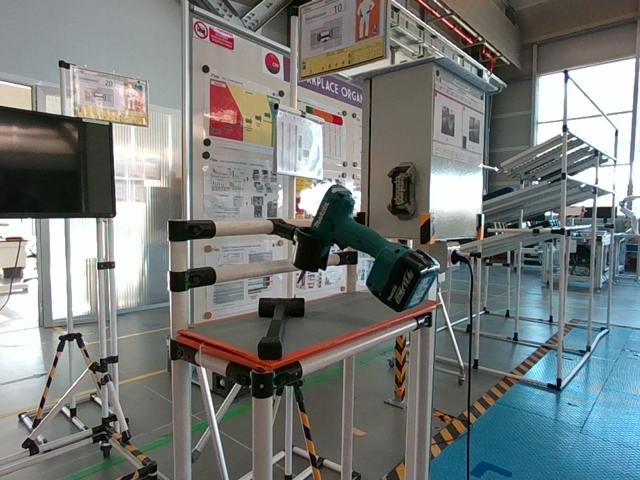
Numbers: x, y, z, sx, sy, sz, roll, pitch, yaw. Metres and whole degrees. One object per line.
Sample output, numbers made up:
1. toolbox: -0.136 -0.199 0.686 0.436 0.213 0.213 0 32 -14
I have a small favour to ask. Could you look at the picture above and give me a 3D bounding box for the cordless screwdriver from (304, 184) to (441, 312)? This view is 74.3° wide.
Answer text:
1. cordless screwdriver: 0.073 0.030 0.740 0.074 0.159 0.248 -7 41 -49
